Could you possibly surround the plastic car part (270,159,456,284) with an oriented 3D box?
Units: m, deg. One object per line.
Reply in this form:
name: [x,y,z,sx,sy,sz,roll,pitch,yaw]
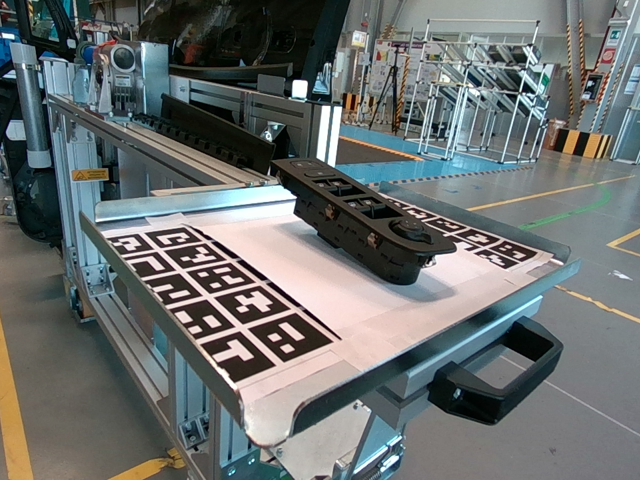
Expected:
plastic car part: [0.029,-0.020,0.408,0.066,0.067,0.204,-3,26,-45]
